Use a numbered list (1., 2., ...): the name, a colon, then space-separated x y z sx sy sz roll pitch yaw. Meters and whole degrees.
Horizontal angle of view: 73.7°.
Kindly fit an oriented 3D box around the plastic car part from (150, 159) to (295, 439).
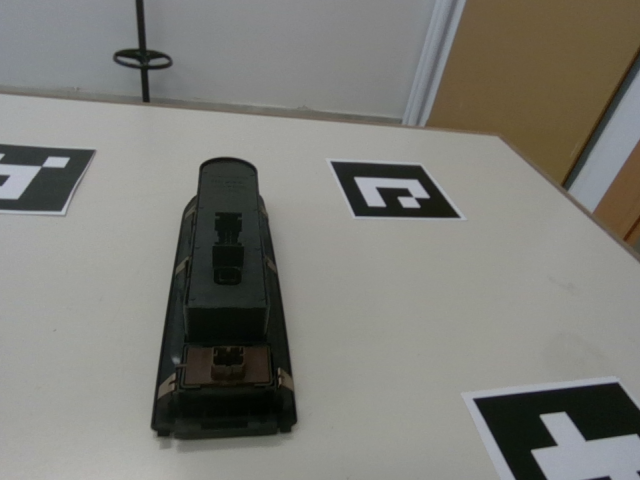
1. plastic car part: -0.060 0.009 0.260 0.066 0.067 0.203 -4 36 -9
